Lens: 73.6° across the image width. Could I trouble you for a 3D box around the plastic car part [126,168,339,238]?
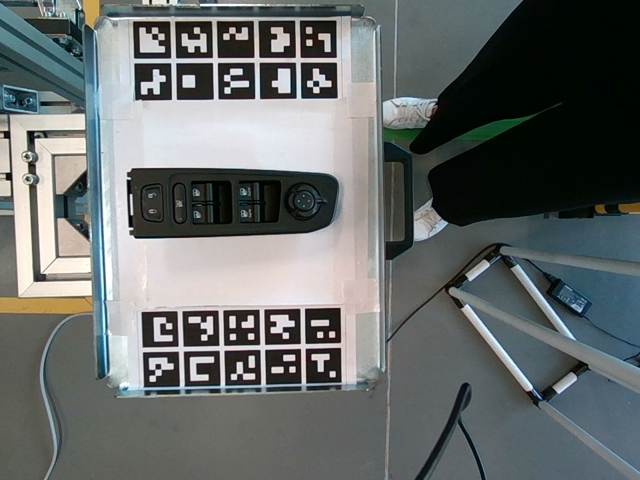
[{"bbox_3d":[-0.082,-0.035,0.435,0.203,0.066,0.067,-2,-6,-5],"label":"plastic car part"}]
